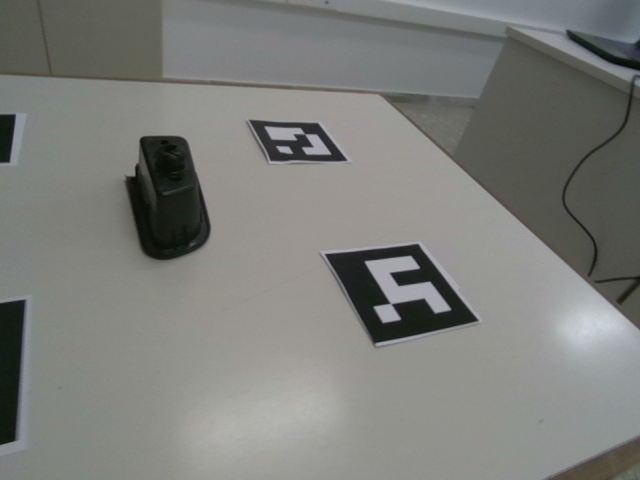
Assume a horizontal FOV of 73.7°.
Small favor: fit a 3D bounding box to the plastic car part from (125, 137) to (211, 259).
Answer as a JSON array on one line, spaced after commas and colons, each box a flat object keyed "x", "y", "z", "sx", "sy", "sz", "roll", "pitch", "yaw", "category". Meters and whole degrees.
[{"x": -0.126, "y": -0.048, "z": 0.359, "sx": 0.065, "sy": 0.071, "sz": 0.117, "roll": -7, "pitch": 39, "yaw": -24, "category": "plastic car part"}]
